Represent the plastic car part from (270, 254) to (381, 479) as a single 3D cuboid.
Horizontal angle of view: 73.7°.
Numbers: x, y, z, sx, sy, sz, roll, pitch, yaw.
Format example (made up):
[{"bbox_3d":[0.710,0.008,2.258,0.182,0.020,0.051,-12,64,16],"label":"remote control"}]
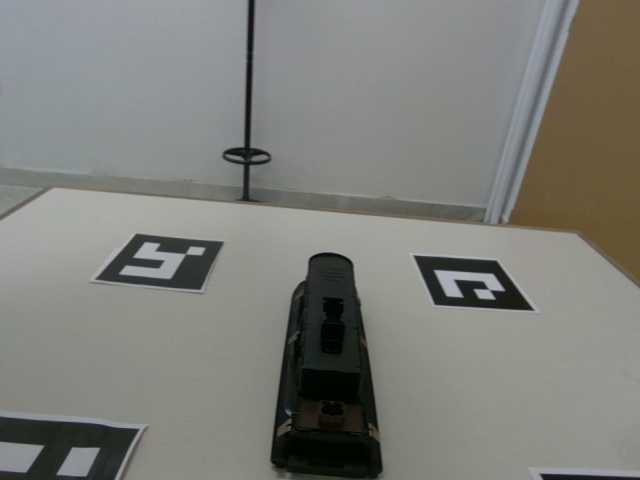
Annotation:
[{"bbox_3d":[0.003,0.070,0.329,0.066,0.067,0.203,-1,24,1],"label":"plastic car part"}]
